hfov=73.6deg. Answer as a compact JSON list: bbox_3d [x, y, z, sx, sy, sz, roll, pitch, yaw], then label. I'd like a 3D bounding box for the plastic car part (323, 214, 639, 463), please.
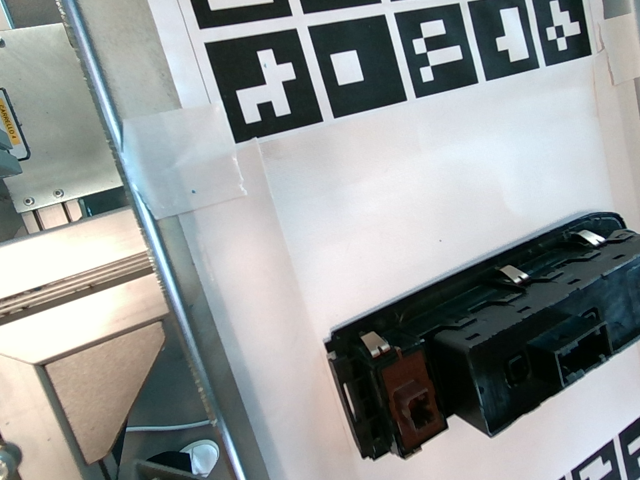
[{"bbox_3d":[0.106,0.036,0.204,0.202,0.066,0.067,-21,2,-24],"label":"plastic car part"}]
